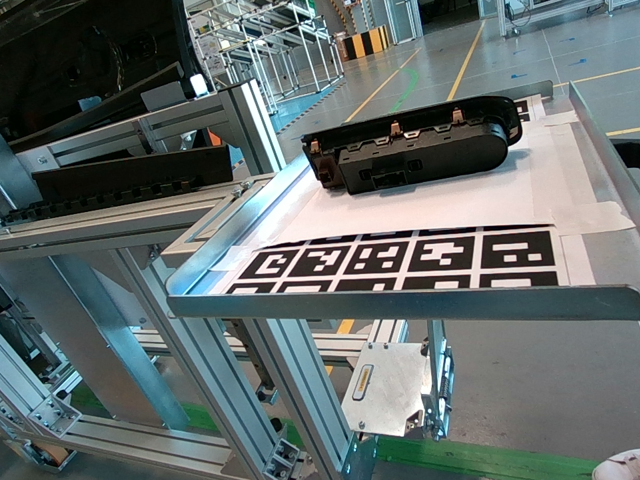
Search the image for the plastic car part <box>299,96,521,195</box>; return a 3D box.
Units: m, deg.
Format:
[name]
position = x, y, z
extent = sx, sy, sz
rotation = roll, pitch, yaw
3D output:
[plastic car part]
position = 0.083, -0.083, 0.400
extent = 0.204, 0.066, 0.067
rotation = -11, 39, 15
